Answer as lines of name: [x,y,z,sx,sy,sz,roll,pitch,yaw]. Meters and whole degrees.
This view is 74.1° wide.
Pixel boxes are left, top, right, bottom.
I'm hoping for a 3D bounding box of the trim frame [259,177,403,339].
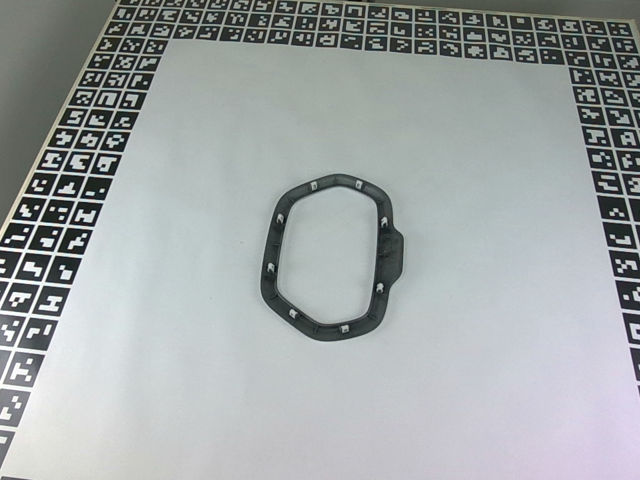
trim frame: [0.016,0.011,0.567,0.184,0.247,0.027,6,-32,4]
